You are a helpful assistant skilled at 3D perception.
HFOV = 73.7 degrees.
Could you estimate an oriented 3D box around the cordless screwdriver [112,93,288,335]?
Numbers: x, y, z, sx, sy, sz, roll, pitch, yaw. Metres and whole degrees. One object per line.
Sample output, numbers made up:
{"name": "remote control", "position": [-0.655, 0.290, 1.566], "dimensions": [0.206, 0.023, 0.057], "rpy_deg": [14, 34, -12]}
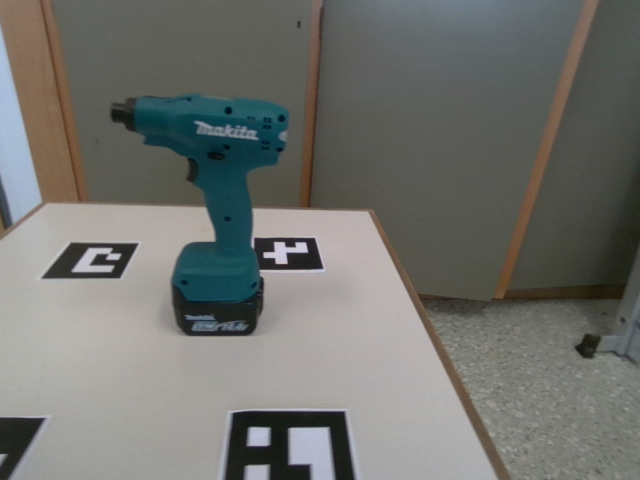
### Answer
{"name": "cordless screwdriver", "position": [-0.124, -0.022, 0.442], "dimensions": [0.159, 0.249, 0.074], "rpy_deg": [6, 26, -6]}
